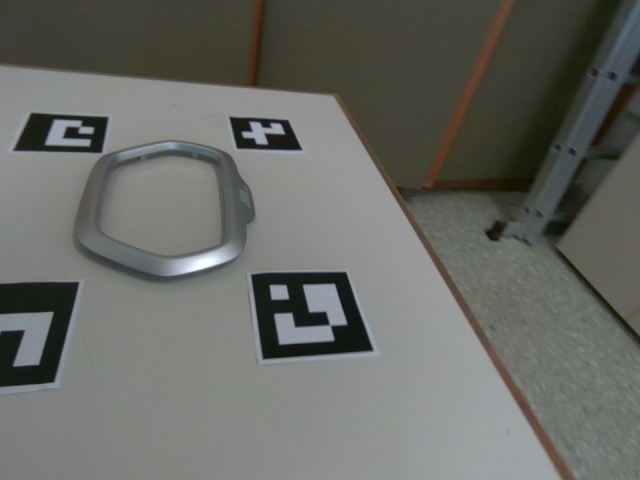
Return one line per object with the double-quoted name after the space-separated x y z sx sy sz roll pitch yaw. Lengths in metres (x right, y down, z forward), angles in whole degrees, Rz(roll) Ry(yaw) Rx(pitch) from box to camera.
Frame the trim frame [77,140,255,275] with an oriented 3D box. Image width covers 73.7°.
-0.168 -0.049 0.487 0.183 0.027 0.249 -3 41 -16 "trim frame"
